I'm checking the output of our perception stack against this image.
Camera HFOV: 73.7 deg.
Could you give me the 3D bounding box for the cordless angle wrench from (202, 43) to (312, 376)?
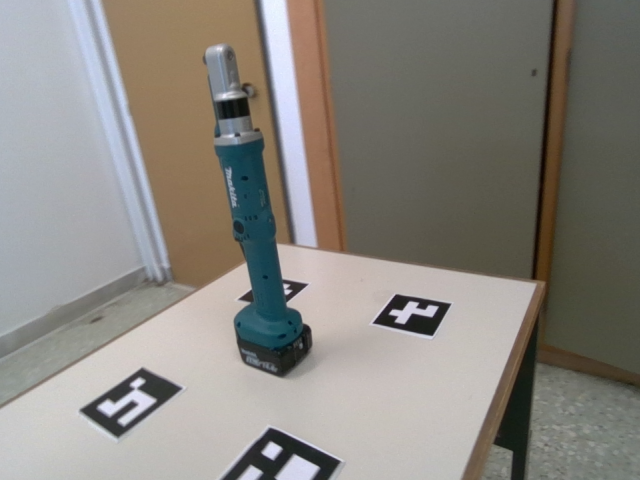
[{"bbox_3d":[-0.088,-0.024,0.554,0.099,0.422,0.073,7,25,34],"label":"cordless angle wrench"}]
